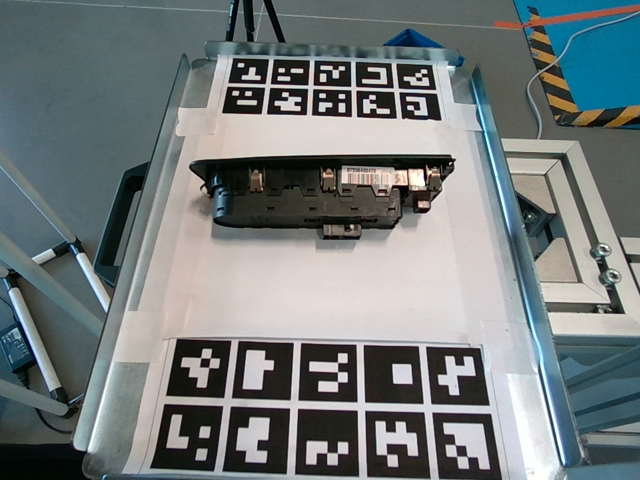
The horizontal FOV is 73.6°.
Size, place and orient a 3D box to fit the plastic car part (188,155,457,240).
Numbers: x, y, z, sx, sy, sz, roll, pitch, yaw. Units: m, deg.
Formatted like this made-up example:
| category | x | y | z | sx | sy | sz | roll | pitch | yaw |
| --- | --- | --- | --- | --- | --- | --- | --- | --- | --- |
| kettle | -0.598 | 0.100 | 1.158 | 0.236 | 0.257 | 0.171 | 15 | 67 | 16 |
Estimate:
| category | x | y | z | sx | sy | sz | roll | pitch | yaw |
| --- | --- | --- | --- | --- | --- | --- | --- | --- | --- |
| plastic car part | -0.002 | -0.034 | 0.344 | 0.203 | 0.067 | 0.066 | 4 | -4 | 1 |
